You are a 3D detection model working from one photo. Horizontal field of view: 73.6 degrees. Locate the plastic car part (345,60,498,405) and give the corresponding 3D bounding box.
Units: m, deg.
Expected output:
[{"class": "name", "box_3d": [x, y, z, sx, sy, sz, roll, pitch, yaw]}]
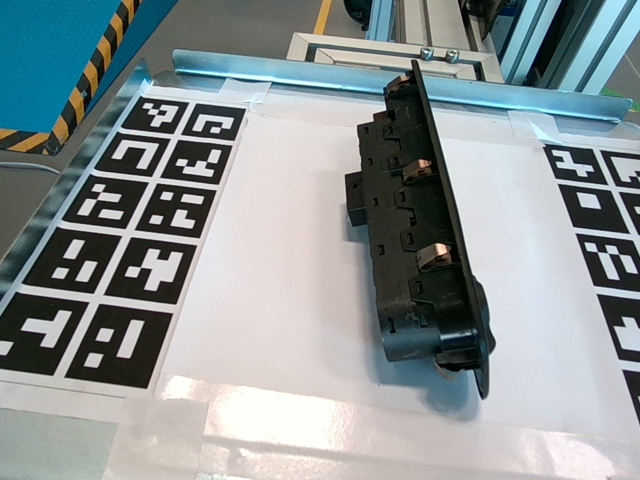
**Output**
[{"class": "plastic car part", "box_3d": [0.049, -0.016, 0.235, 0.067, 0.202, 0.066, -8, -39, 4]}]
